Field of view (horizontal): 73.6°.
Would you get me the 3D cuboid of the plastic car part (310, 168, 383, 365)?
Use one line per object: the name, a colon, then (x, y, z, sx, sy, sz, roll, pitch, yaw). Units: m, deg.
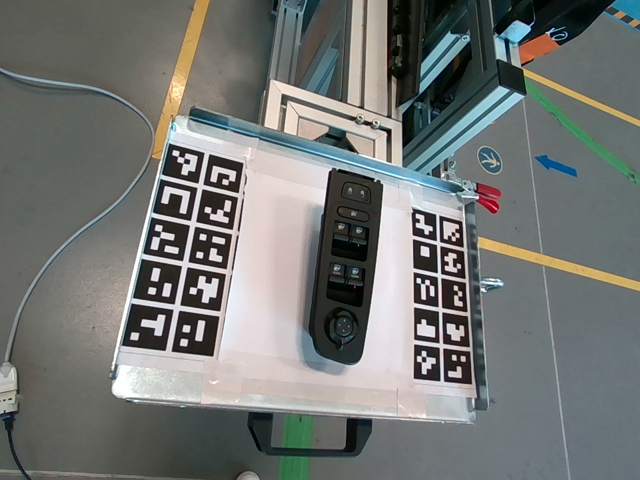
plastic car part: (0.020, 0.029, 0.464, 0.066, 0.202, 0.067, 14, -20, -26)
